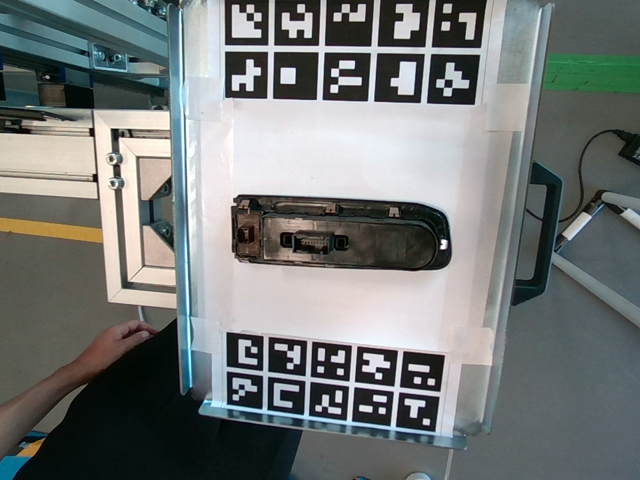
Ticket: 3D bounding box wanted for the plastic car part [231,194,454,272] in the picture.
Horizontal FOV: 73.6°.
[{"bbox_3d":[0.016,-0.004,0.372,0.203,0.066,0.067,3,6,6],"label":"plastic car part"}]
